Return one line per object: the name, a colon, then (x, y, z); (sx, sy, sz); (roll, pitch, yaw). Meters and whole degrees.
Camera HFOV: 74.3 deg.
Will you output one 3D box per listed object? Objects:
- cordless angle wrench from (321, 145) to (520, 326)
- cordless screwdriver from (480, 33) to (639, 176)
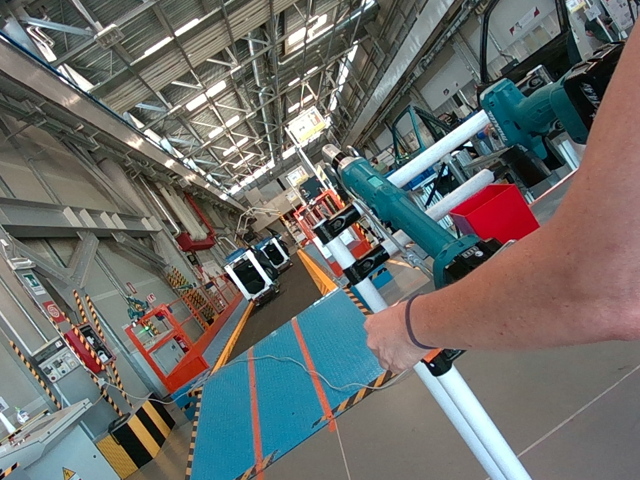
cordless angle wrench: (0.106, -0.052, 0.632); (0.074, 0.098, 0.422); (-31, 44, -9)
cordless screwdriver: (0.318, -0.154, 0.551); (0.074, 0.159, 0.248); (-36, 12, -2)
